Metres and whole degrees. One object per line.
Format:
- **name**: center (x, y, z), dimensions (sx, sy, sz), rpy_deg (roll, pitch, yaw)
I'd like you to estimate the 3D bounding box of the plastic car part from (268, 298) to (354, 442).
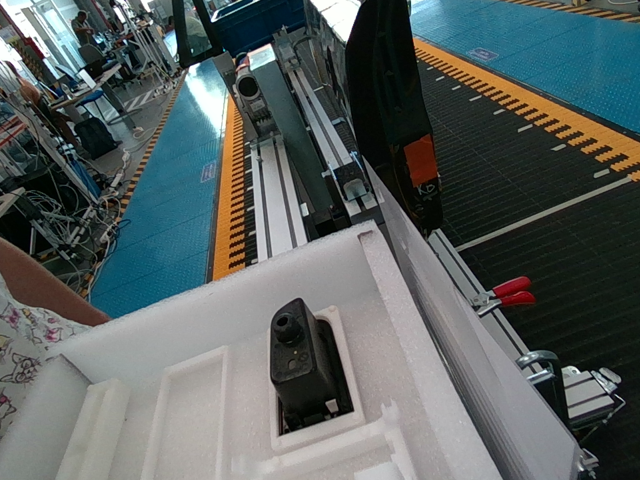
- **plastic car part**: center (-0.020, 0.099, 0.372), dimensions (0.066, 0.071, 0.116), rpy_deg (-20, 38, 5)
